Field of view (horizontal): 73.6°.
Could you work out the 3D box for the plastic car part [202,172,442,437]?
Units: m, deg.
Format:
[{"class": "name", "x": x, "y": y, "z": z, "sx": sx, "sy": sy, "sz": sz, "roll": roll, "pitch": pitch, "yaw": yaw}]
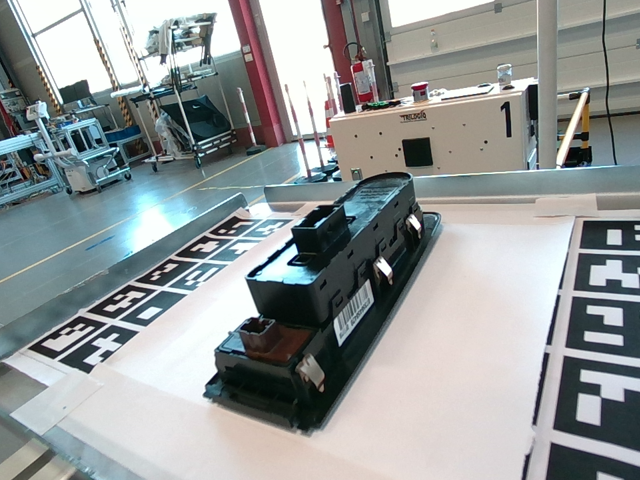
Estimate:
[{"class": "plastic car part", "x": 0.014, "y": 0.010, "z": 0.249, "sx": 0.067, "sy": 0.067, "sz": 0.201, "roll": -6, "pitch": 21, "yaw": 36}]
